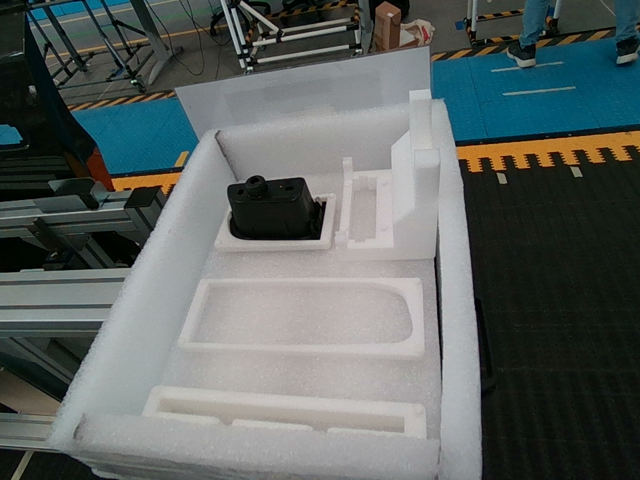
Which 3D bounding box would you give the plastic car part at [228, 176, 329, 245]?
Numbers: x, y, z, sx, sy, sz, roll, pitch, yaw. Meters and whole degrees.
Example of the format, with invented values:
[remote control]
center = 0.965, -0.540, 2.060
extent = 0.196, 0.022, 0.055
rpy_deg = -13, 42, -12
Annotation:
[plastic car part]
center = -0.055, -0.038, 0.470
extent = 0.117, 0.066, 0.071
rpy_deg = 1, -44, 13
